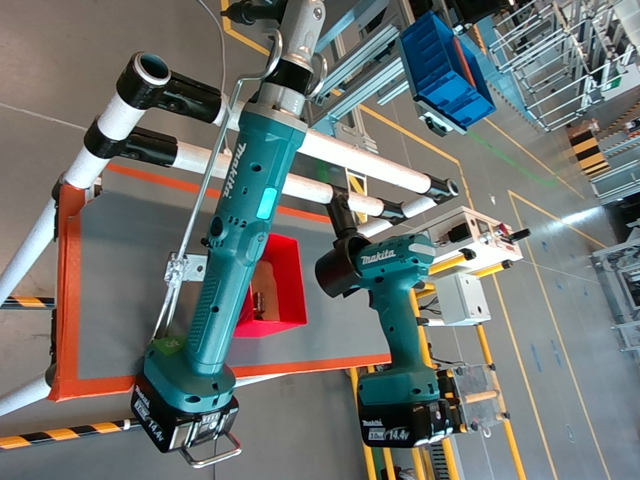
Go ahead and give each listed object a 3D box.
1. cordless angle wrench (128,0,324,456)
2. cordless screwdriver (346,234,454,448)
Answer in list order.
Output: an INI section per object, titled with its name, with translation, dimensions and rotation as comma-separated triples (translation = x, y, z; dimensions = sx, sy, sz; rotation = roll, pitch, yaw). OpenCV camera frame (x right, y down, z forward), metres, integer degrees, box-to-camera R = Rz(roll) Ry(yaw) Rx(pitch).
[cordless angle wrench]
translation = -0.077, -0.009, 0.391
dimensions = 0.098, 0.423, 0.074
rotation = 28, 13, 37
[cordless screwdriver]
translation = 0.079, 0.126, 0.542
dimensions = 0.074, 0.248, 0.159
rotation = 12, -21, -41
